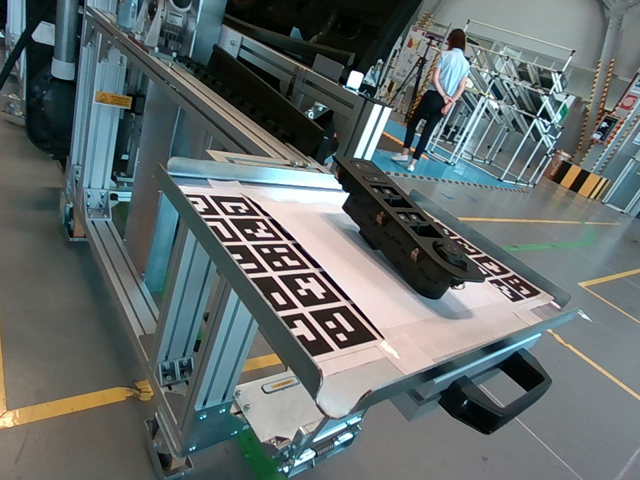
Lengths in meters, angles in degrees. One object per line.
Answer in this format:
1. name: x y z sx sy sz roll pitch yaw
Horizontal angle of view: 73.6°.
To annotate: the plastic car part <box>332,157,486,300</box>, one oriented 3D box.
1. plastic car part: 0.079 -0.012 0.449 0.066 0.067 0.203 7 32 -48
